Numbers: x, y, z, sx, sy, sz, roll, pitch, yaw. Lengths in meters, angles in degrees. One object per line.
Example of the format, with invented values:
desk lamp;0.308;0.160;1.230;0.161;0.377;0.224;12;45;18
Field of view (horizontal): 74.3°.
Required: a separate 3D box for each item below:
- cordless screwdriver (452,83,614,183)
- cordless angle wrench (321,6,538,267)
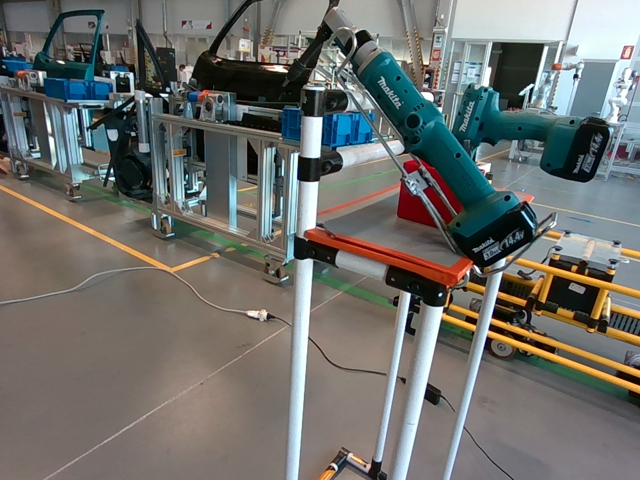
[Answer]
cordless screwdriver;0.344;-0.160;0.726;0.249;0.159;0.074;29;29;29
cordless angle wrench;0.135;-0.160;0.587;0.098;0.422;0.074;-39;-8;31
